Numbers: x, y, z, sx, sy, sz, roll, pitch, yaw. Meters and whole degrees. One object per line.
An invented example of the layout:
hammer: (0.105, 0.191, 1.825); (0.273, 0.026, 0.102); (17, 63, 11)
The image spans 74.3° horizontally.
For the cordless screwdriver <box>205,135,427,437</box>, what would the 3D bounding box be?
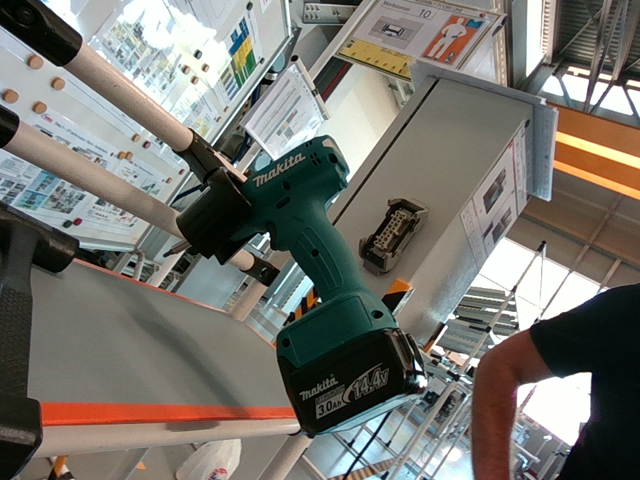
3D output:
cordless screwdriver: (-0.021, 0.037, 0.367); (0.159, 0.248, 0.074); (-27, -28, 14)
